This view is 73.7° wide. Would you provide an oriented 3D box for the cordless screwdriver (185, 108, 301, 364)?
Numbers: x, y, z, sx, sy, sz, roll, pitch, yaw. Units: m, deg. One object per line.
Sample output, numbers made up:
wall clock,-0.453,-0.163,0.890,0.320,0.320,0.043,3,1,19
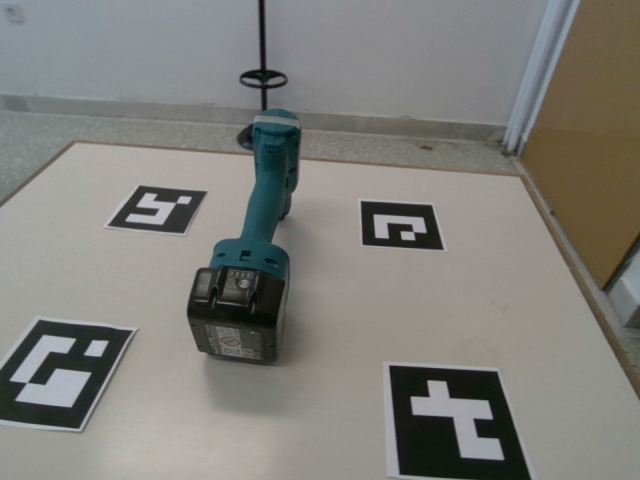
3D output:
cordless screwdriver,-0.061,0.002,0.443,0.074,0.248,0.159,8,-35,0
